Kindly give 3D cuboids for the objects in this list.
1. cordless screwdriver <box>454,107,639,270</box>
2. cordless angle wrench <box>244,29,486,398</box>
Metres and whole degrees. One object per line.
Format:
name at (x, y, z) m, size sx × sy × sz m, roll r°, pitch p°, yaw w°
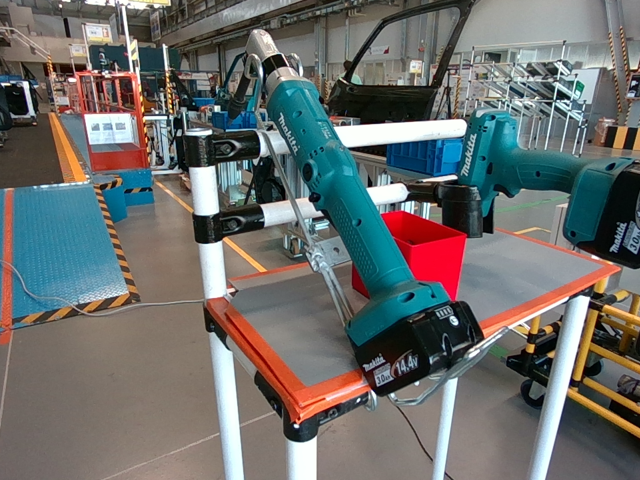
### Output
cordless screwdriver at (0.253, -0.045, 0.474) m, size 0.074 × 0.159 × 0.248 m, roll -11°, pitch 31°, yaw -28°
cordless angle wrench at (0.008, -0.065, 0.426) m, size 0.074 × 0.422 × 0.098 m, roll -9°, pitch -26°, yaw -37°
